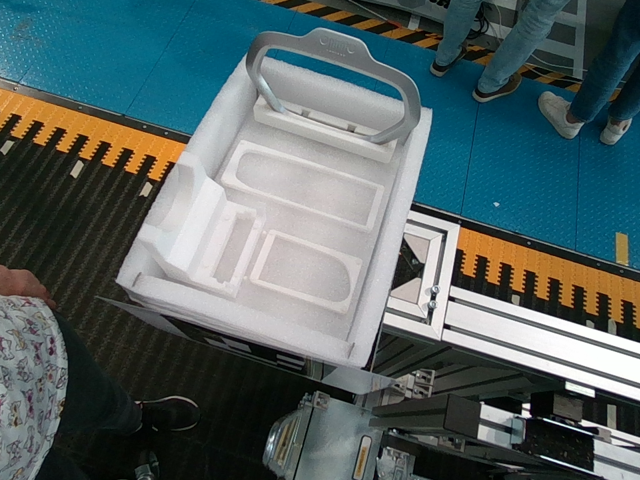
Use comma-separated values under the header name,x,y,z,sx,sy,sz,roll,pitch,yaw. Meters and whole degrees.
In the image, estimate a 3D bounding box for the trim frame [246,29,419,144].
name,x,y,z,sx,sy,sz,roll,pitch,yaw
trim frame,0.015,-0.204,0.583,0.249,0.027,0.184,20,-19,4
